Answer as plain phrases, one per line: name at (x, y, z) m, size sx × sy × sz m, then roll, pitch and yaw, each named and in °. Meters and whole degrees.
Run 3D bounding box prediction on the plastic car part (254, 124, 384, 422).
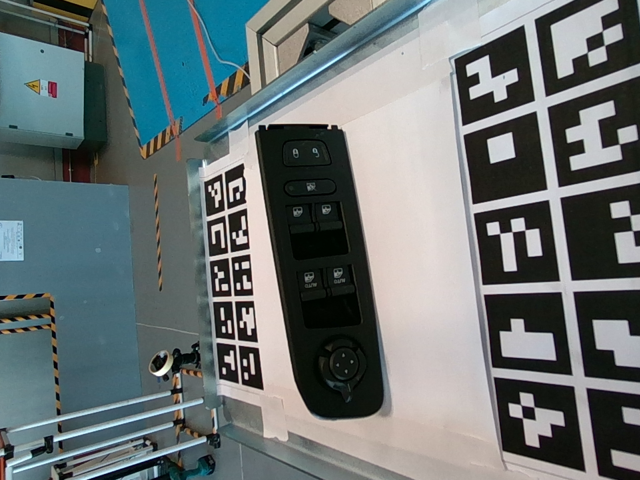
plastic car part at (-0.008, 0.023, 0.301) m, size 0.066 × 0.202 × 0.067 m, roll -5°, pitch -14°, yaw -32°
